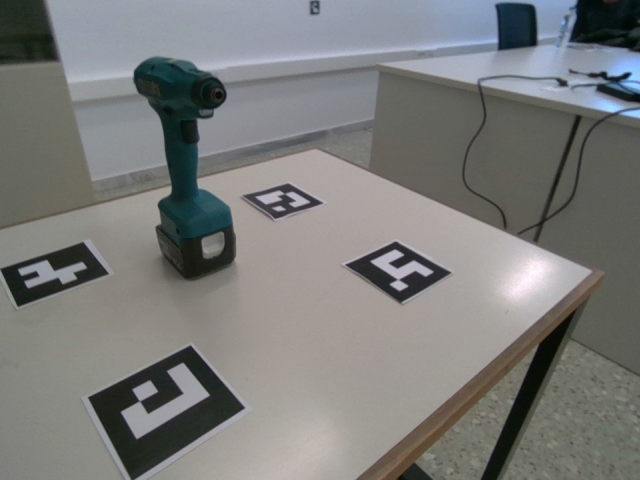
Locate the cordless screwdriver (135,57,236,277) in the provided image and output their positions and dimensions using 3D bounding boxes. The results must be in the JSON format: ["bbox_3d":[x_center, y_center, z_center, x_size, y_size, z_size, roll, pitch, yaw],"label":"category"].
[{"bbox_3d":[-0.145,-0.075,0.495,0.073,0.248,0.161,-21,34,-34],"label":"cordless screwdriver"}]
